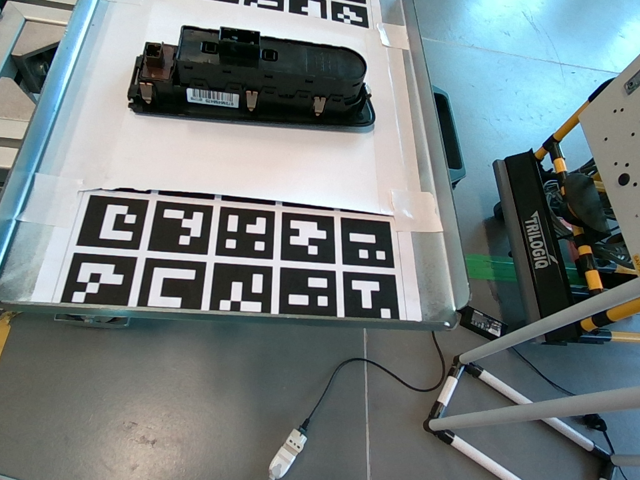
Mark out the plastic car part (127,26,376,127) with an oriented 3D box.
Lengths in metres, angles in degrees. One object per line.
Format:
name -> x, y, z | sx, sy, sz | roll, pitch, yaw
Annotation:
plastic car part -> -0.048, -0.136, 0.349 | 0.202, 0.066, 0.067 | 5, -35, -12
